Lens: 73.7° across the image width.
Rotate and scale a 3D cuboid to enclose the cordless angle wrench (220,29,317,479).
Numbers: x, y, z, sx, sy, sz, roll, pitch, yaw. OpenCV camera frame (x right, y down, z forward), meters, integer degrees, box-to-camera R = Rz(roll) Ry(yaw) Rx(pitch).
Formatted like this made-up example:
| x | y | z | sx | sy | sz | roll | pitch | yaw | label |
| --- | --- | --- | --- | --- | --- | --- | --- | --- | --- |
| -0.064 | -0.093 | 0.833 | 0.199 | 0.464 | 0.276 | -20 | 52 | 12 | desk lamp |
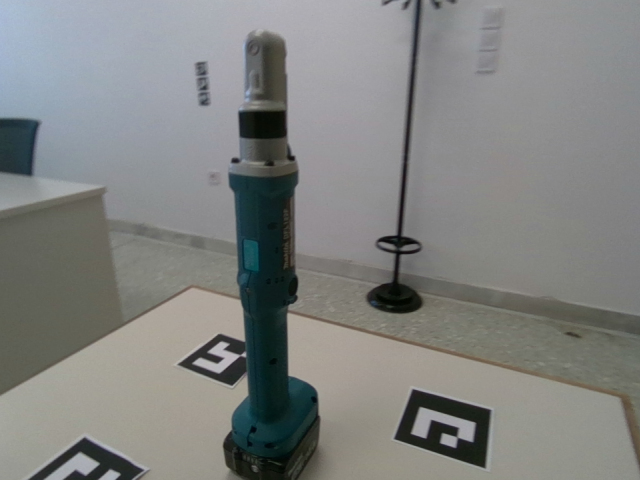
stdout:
| x | y | z | sx | sy | sz | roll | pitch | yaw | label |
| --- | --- | --- | --- | --- | --- | --- | --- | --- | --- |
| -0.049 | 0.038 | 0.397 | 0.075 | 0.423 | 0.097 | 10 | 21 | 24 | cordless angle wrench |
